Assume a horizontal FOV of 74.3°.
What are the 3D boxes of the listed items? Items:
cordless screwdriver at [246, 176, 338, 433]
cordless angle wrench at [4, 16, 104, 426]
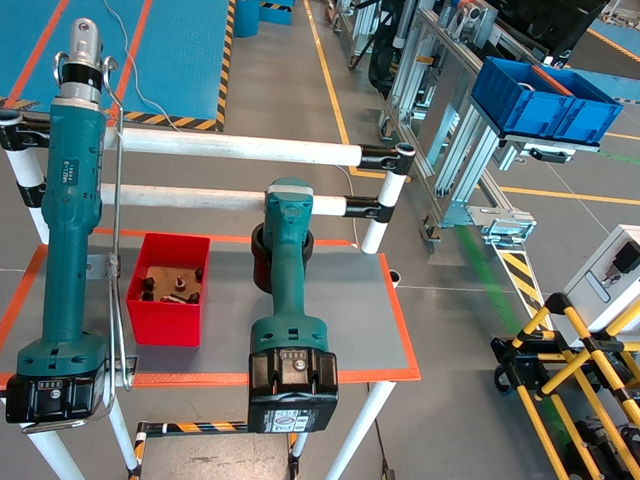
[{"bbox_3d":[-0.038,0.071,0.452,0.074,0.248,0.160,3,-37,-9],"label":"cordless screwdriver"},{"bbox_3d":[-0.267,-0.033,0.450,0.074,0.422,0.098,4,-5,-27],"label":"cordless angle wrench"}]
